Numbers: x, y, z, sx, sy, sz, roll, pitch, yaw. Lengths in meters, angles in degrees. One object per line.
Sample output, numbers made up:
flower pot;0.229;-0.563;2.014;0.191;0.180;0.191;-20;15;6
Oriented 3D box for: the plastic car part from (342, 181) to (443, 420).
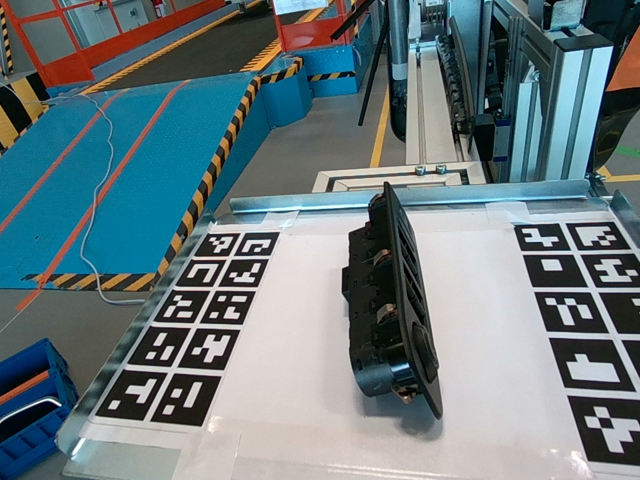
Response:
plastic car part;0.049;0.035;0.324;0.067;0.066;0.202;-18;34;13
